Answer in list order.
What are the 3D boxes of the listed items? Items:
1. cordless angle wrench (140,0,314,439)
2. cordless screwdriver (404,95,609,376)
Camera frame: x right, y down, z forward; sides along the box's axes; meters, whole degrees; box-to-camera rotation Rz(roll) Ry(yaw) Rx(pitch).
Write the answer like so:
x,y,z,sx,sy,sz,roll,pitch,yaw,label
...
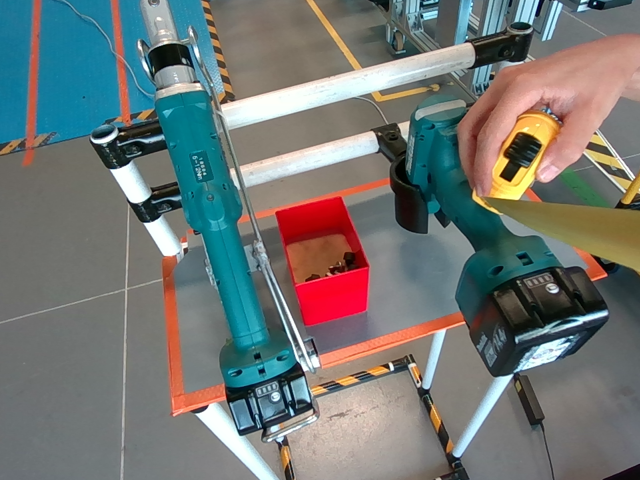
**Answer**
x,y,z,sx,sy,sz,roll,pitch,yaw,label
-0.103,-0.032,0.410,0.074,0.423,0.098,-16,1,-12,cordless angle wrench
0.144,0.000,0.405,0.074,0.248,0.159,-15,-31,-4,cordless screwdriver
